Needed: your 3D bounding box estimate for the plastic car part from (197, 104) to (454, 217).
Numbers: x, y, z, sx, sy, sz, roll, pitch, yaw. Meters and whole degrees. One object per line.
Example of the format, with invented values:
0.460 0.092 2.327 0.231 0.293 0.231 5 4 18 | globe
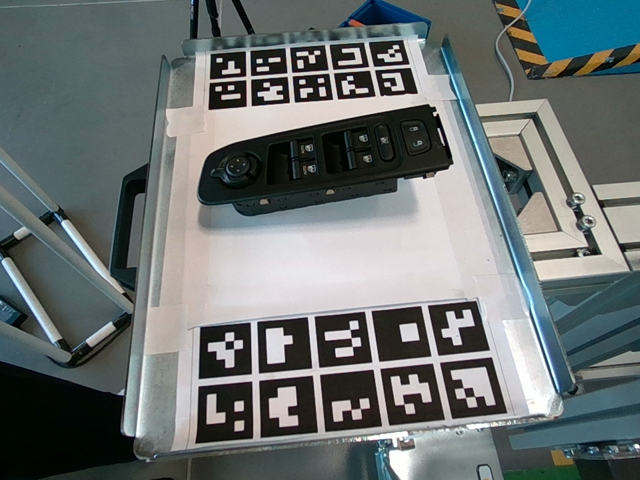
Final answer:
-0.001 -0.060 0.362 0.203 0.066 0.067 -8 -20 1 | plastic car part
